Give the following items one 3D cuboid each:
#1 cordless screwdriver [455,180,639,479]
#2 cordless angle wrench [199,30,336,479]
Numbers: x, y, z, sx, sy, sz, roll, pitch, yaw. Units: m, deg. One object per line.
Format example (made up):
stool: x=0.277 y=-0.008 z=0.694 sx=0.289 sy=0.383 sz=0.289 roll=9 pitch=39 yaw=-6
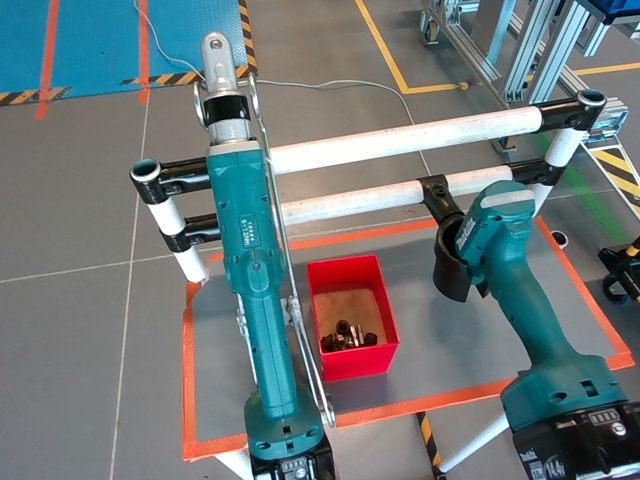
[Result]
cordless screwdriver: x=0.184 y=0.086 z=0.386 sx=0.074 sy=0.248 sz=0.159 roll=-9 pitch=-30 yaw=-3
cordless angle wrench: x=-0.060 y=0.025 z=0.394 sx=0.074 sy=0.423 sz=0.098 roll=-11 pitch=6 yaw=-10
